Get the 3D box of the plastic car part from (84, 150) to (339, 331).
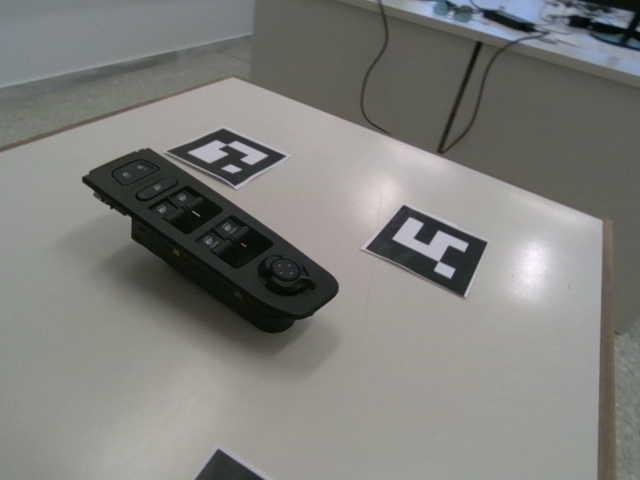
[{"bbox_3d":[-0.084,0.006,0.326,0.204,0.067,0.066,29,35,17],"label":"plastic car part"}]
